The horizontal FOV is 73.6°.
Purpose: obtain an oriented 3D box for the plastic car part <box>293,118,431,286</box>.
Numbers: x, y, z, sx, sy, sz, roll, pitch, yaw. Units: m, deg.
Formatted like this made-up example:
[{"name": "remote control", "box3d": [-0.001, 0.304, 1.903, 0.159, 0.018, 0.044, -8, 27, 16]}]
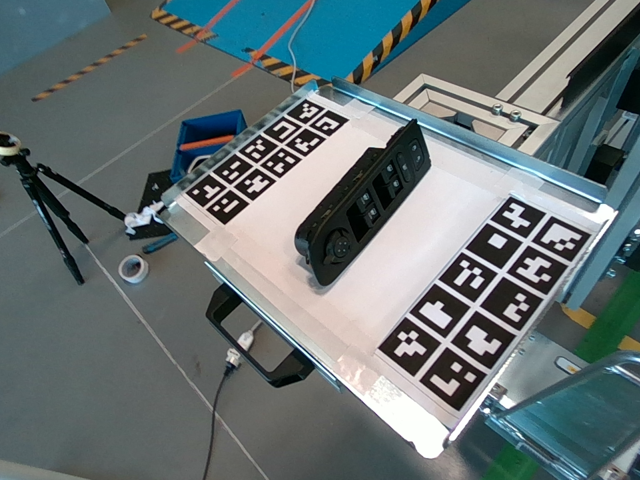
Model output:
[{"name": "plastic car part", "box3d": [0.039, -0.044, 0.448, 0.067, 0.202, 0.066, 18, -31, 36]}]
